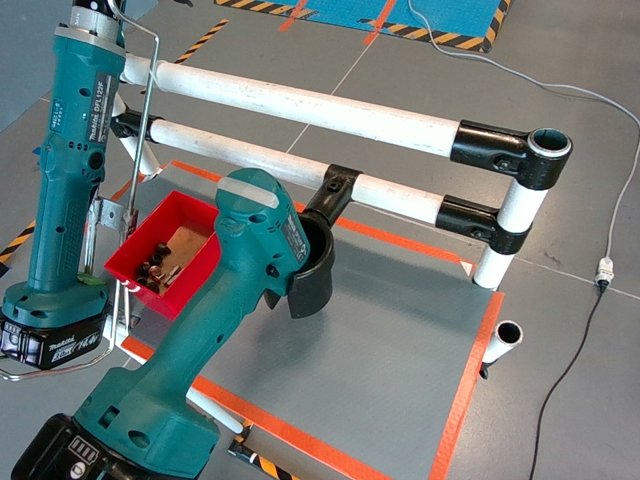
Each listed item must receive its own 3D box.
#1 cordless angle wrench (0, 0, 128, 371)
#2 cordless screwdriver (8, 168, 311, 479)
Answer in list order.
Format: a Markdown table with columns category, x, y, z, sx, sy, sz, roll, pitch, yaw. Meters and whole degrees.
| category | x | y | z | sx | sy | sz | roll | pitch | yaw |
| --- | --- | --- | --- | --- | --- | --- | --- | --- | --- |
| cordless angle wrench | -0.238 | -0.083 | 0.416 | 0.074 | 0.423 | 0.098 | 18 | 11 | 14 |
| cordless screwdriver | -0.081 | 0.084 | 0.319 | 0.074 | 0.248 | 0.159 | 20 | -23 | 22 |
